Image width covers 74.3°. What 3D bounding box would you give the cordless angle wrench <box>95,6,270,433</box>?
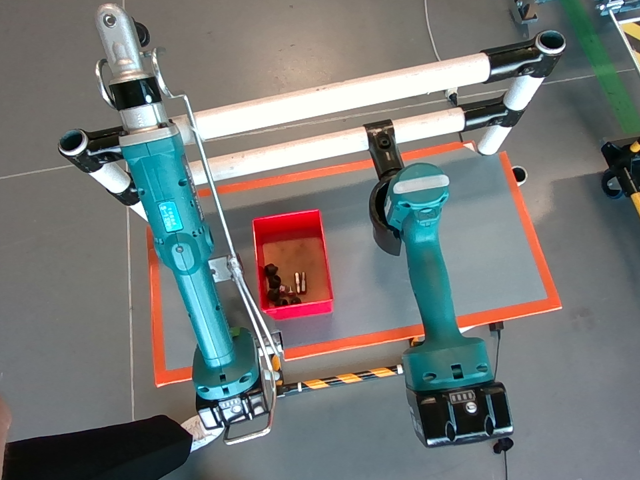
[{"bbox_3d":[-0.135,0.001,0.425,0.074,0.423,0.098,-13,21,-4],"label":"cordless angle wrench"}]

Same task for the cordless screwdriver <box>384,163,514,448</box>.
[{"bbox_3d":[0.109,0.062,0.424,0.074,0.248,0.159,-9,-11,3],"label":"cordless screwdriver"}]
